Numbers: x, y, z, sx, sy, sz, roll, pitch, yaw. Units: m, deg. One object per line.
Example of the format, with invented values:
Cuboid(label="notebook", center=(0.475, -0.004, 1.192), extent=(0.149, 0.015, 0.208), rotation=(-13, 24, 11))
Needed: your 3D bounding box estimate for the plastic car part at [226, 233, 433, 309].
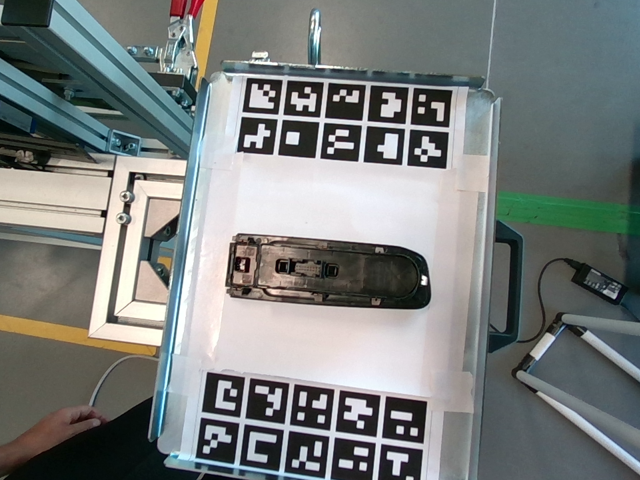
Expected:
Cuboid(label="plastic car part", center=(0.008, 0.028, 0.405), extent=(0.203, 0.066, 0.067), rotation=(5, -12, 3))
